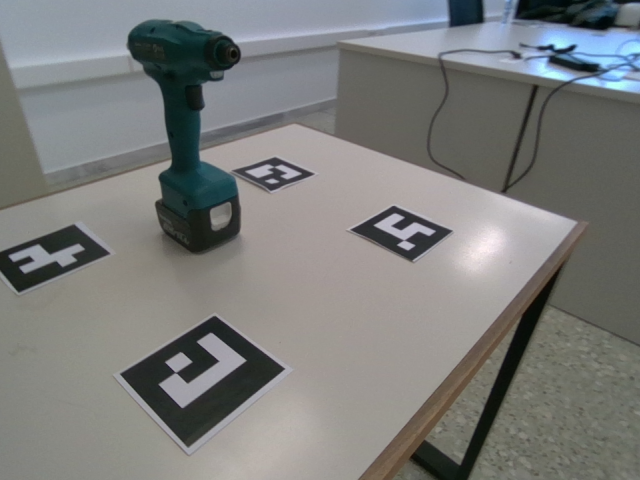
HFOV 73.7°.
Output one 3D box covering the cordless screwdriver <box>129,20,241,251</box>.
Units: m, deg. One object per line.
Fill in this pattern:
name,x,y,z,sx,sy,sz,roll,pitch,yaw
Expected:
cordless screwdriver,-0.136,-0.107,0.480,0.161,0.248,0.073,25,38,37
